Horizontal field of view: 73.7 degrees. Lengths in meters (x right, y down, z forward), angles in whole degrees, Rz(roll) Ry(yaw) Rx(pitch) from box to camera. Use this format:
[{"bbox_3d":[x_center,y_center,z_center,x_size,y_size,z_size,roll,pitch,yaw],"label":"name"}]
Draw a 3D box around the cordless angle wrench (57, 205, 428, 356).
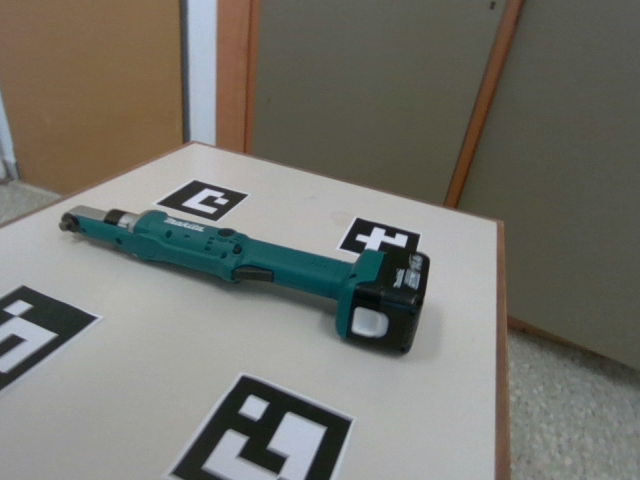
[{"bbox_3d":[-0.103,0.017,0.469,0.425,0.074,0.097,13,31,14],"label":"cordless angle wrench"}]
